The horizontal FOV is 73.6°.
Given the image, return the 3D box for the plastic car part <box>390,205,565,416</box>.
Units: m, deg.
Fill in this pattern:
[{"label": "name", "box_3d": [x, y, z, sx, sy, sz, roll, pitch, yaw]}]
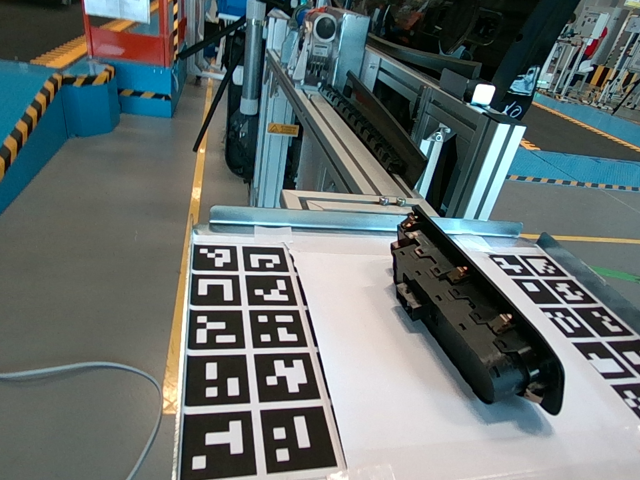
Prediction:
[{"label": "plastic car part", "box_3d": [0.106, 0.050, 0.343, 0.067, 0.066, 0.203, -16, 38, -16]}]
